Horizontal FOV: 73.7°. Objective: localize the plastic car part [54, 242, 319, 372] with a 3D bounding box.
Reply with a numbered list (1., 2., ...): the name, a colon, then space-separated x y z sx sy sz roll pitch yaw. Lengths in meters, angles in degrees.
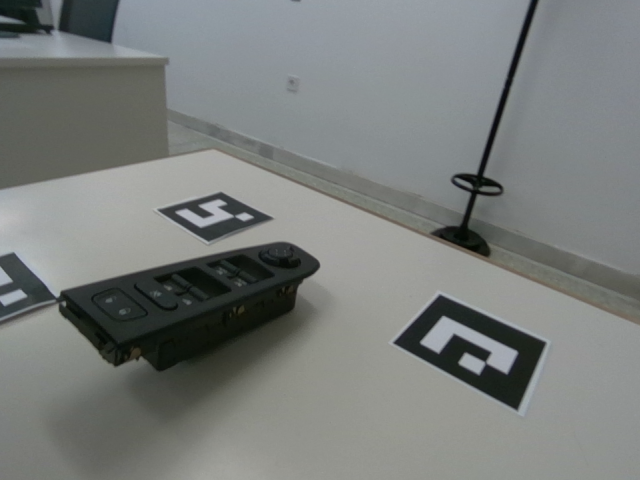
1. plastic car part: -0.074 0.047 0.319 0.067 0.067 0.201 17 25 34
